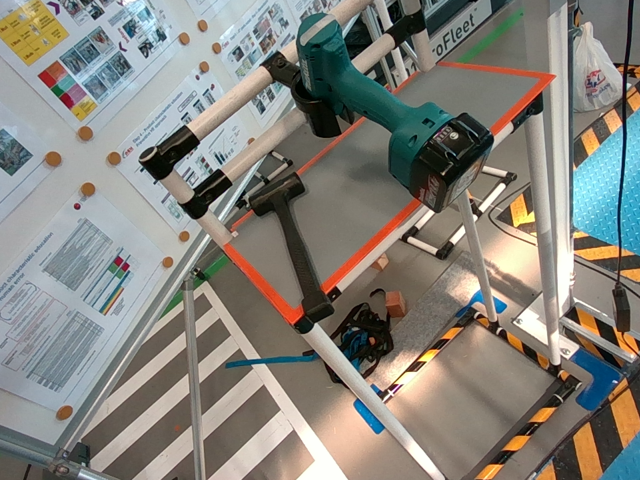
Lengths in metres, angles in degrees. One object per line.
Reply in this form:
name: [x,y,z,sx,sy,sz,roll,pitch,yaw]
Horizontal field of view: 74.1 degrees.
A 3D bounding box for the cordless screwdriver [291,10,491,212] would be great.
cordless screwdriver: [0.067,-0.139,0.498,0.074,0.249,0.159,-43,-16,-8]
